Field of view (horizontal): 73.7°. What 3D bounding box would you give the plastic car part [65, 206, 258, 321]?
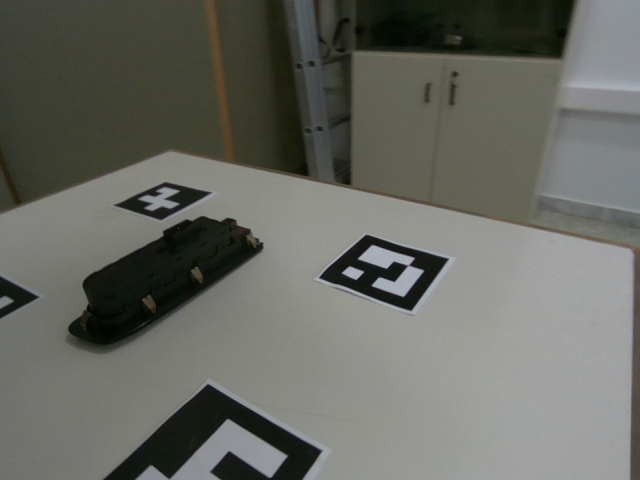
[{"bbox_3d":[-0.154,0.021,0.436,0.201,0.066,0.067,-38,-15,-32],"label":"plastic car part"}]
